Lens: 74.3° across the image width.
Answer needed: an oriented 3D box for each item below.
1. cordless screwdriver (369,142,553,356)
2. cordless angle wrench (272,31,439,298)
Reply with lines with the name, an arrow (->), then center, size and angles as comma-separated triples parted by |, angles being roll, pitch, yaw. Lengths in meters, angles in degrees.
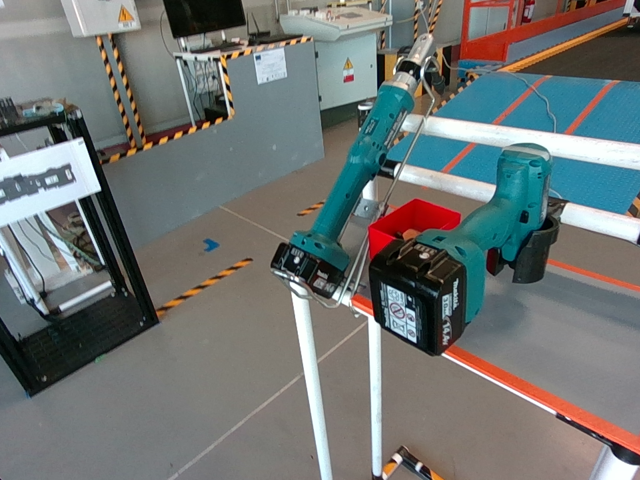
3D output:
cordless screwdriver -> 0.162, 0.019, 0.442 | 0.248, 0.159, 0.074 | -37, 41, -28
cordless angle wrench -> 0.070, -0.122, 0.625 | 0.074, 0.422, 0.098 | 25, -4, 35
